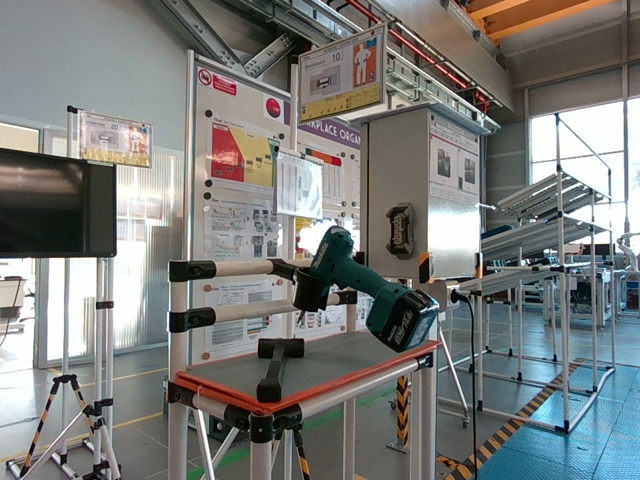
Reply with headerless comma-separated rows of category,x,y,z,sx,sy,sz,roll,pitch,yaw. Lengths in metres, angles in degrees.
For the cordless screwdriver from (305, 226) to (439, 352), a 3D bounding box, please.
cordless screwdriver,0.072,0.101,0.743,0.074,0.159,0.248,-1,32,-49
